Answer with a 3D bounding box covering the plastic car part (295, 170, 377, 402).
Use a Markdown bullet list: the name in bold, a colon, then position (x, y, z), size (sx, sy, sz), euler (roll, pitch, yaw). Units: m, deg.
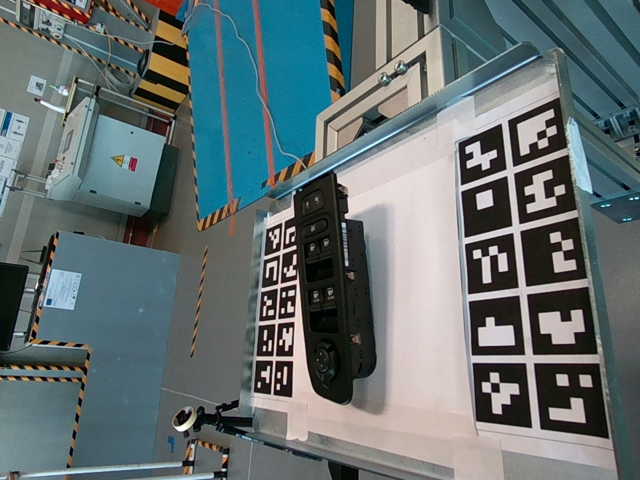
- **plastic car part**: position (0.016, 0.044, 0.400), size (0.067, 0.202, 0.067), euler (14, -21, -43)
